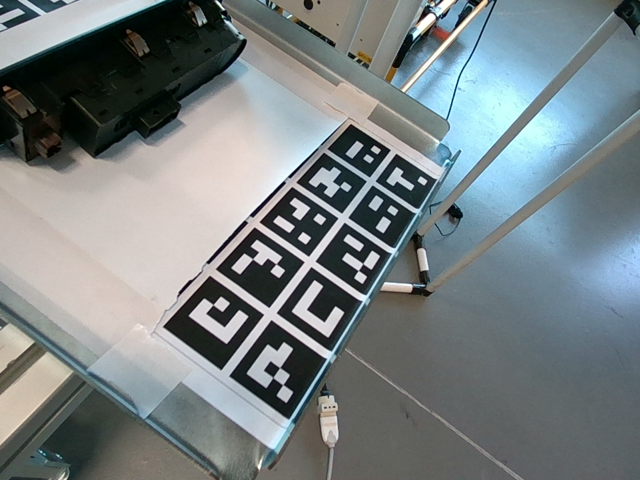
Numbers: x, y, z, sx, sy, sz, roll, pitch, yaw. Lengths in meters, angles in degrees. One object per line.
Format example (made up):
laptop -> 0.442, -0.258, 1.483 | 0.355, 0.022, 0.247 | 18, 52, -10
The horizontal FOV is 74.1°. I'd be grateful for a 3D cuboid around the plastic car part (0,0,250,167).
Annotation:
plastic car part -> -0.115, -0.111, 0.286 | 0.067, 0.202, 0.067 | 36, -34, -2
